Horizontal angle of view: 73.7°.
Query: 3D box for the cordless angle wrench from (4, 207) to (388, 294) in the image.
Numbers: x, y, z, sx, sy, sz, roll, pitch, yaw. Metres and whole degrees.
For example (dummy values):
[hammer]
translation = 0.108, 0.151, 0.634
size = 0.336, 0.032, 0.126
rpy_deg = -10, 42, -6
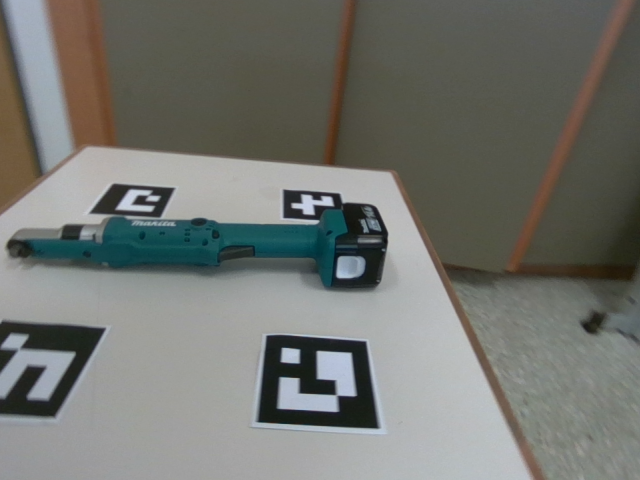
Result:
[cordless angle wrench]
translation = -0.139, 0.010, 0.499
size = 0.422, 0.074, 0.098
rpy_deg = 1, 33, -4
